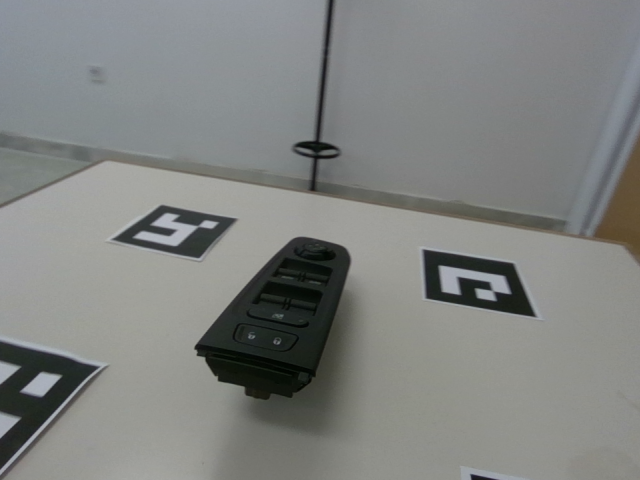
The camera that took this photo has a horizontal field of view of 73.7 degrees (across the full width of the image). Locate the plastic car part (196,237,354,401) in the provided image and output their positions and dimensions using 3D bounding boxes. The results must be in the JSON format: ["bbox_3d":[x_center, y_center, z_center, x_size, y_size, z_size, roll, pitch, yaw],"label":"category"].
[{"bbox_3d":[-0.014,0.051,0.318,0.066,0.067,0.202,3,24,12],"label":"plastic car part"}]
